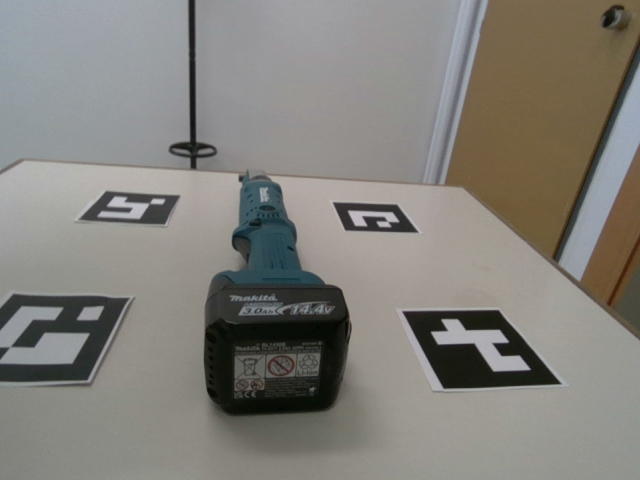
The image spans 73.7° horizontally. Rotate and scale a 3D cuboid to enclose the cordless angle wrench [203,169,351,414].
[{"bbox_3d":[-0.060,-0.007,0.454,0.097,0.074,0.424,1,25,-11],"label":"cordless angle wrench"}]
